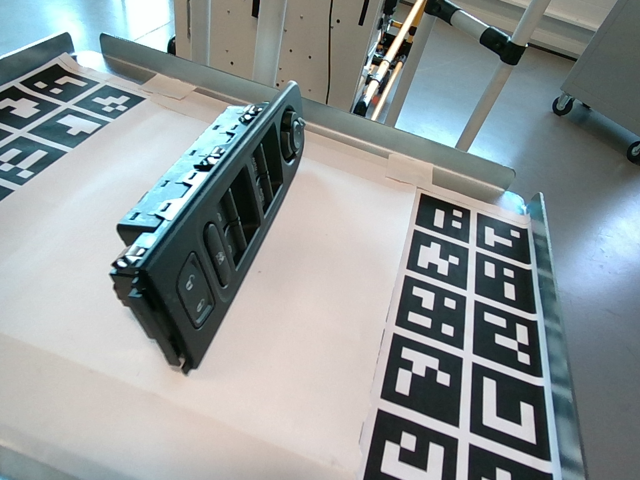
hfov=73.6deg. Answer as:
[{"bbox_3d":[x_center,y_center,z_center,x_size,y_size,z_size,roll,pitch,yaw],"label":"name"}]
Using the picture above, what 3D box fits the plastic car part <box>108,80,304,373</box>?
[{"bbox_3d":[-0.057,-0.029,0.251,0.068,0.067,0.202,2,42,23],"label":"plastic car part"}]
